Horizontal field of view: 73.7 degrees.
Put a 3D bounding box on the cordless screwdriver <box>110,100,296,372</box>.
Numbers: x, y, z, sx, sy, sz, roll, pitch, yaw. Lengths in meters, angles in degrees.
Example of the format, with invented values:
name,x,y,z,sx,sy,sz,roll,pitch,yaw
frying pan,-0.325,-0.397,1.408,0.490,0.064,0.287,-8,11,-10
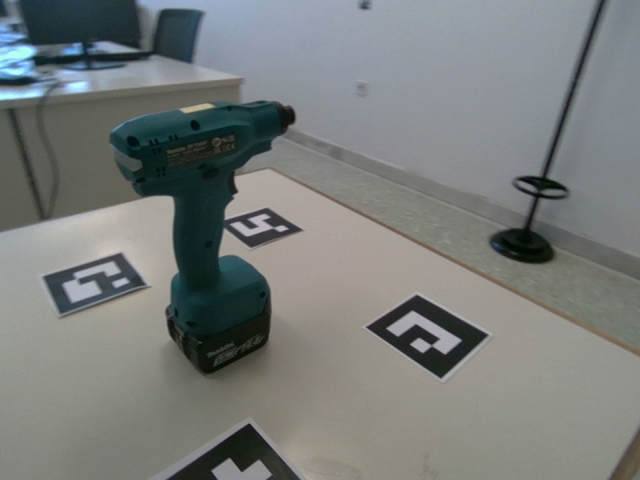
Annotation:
name,x,y,z,sx,sy,sz,roll,pitch,yaw
cordless screwdriver,-0.087,-0.005,0.409,0.158,0.248,0.075,-24,40,-33
